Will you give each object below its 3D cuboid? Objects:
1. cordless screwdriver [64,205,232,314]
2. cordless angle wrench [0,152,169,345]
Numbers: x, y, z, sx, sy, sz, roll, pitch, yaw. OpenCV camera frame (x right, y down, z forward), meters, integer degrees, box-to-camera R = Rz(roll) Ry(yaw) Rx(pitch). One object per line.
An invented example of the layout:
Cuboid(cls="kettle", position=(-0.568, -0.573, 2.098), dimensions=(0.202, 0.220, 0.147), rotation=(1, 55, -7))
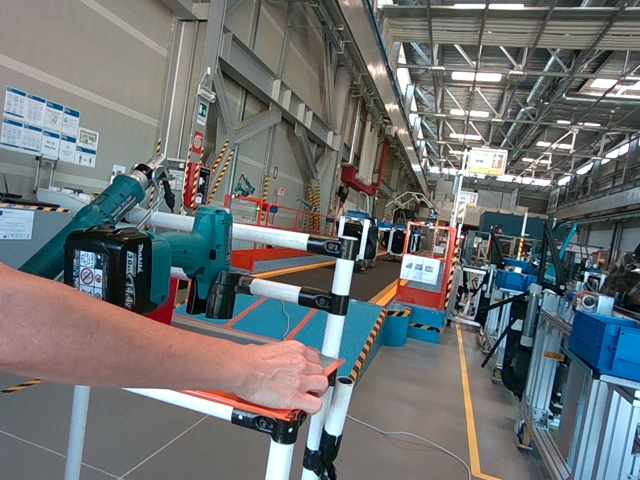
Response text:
Cuboid(cls="cordless screwdriver", position=(-0.194, 0.042, 0.545), dimensions=(0.074, 0.159, 0.248), rotation=(7, 11, 19))
Cuboid(cls="cordless angle wrench", position=(-0.381, -0.027, 0.710), dimensions=(0.074, 0.098, 0.421), rotation=(12, 47, 15))
